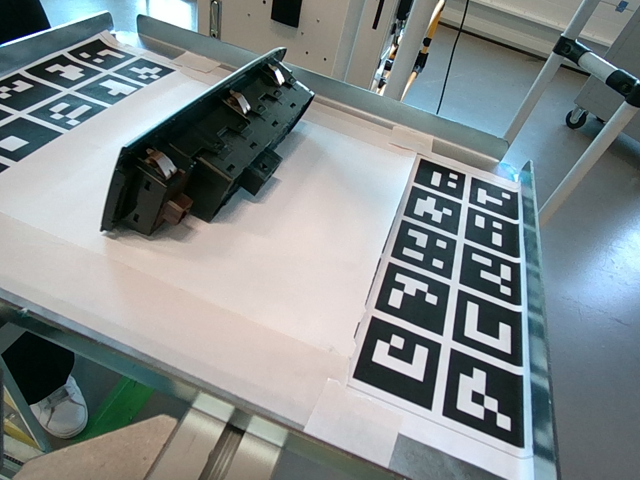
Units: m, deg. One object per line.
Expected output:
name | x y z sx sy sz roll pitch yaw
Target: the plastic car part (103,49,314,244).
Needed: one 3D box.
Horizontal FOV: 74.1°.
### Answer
plastic car part | -0.052 -0.069 0.276 0.067 0.066 0.202 23 43 -1
